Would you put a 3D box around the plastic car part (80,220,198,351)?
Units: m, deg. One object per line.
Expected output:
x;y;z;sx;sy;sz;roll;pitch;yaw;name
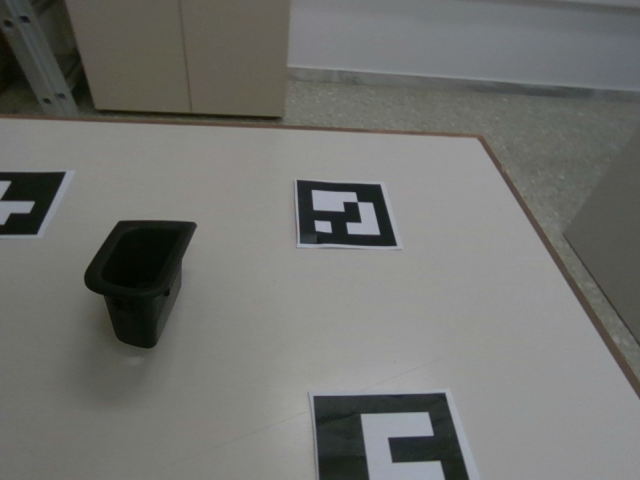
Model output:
-0.135;0.038;0.326;0.066;0.071;0.117;2;29;-6;plastic car part
